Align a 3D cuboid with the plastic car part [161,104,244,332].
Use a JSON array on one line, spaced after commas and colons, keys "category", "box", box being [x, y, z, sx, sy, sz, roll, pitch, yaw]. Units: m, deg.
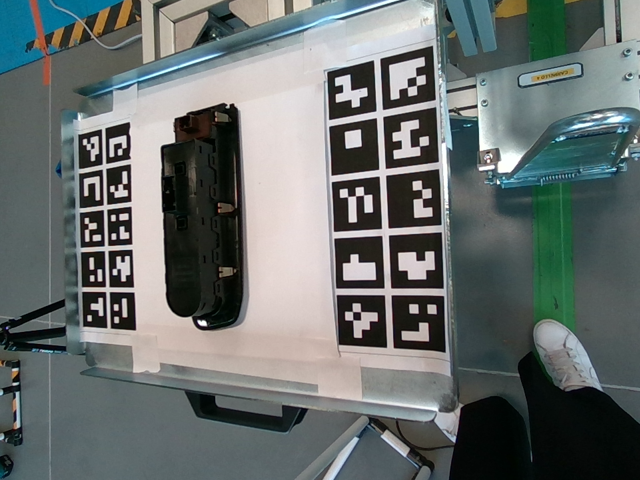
[{"category": "plastic car part", "box": [-0.104, -0.018, 0.369, 0.067, 0.203, 0.067, -5, 0, 20]}]
